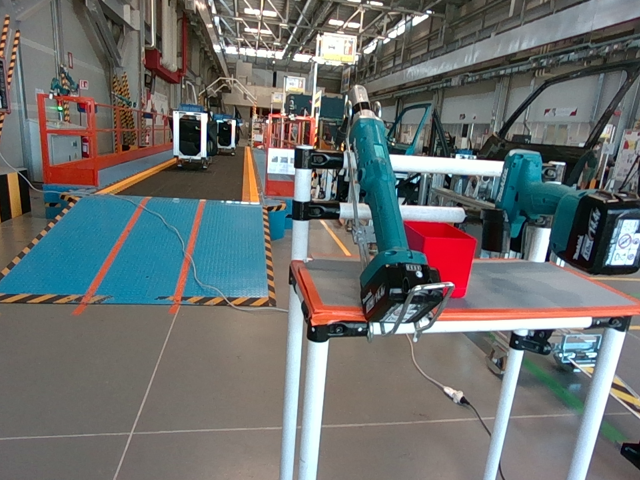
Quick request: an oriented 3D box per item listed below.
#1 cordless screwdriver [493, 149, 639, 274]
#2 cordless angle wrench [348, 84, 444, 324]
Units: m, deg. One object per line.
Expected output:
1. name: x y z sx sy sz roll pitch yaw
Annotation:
1. cordless screwdriver: 0.324 -0.024 0.591 0.074 0.159 0.248 0 24 -9
2. cordless angle wrench: 0.083 -0.088 0.626 0.074 0.421 0.098 6 -34 -18
